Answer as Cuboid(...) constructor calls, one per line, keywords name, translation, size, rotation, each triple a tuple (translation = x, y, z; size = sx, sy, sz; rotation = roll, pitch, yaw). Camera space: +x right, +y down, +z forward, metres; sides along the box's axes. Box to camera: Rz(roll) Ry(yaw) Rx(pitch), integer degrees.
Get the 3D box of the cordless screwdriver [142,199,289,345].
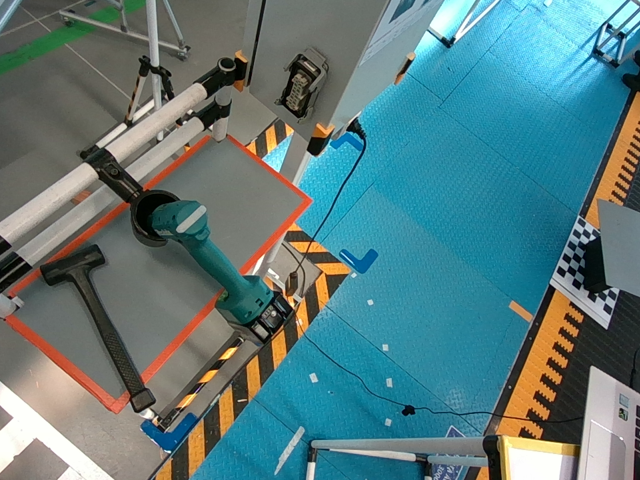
Cuboid(name="cordless screwdriver", translation=(-0.165, 0.043, 0.639), size=(0.160, 0.248, 0.074), rotation=(3, 45, 52))
